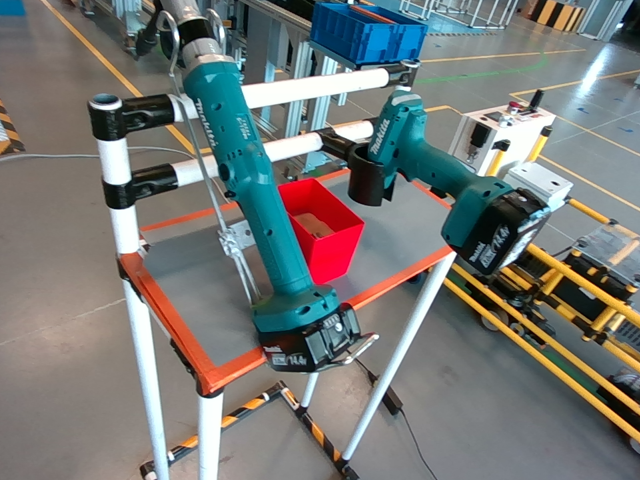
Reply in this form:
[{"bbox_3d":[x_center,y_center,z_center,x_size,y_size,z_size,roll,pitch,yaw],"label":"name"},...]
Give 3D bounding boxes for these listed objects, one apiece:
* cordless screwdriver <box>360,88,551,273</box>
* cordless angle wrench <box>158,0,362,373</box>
[{"bbox_3d":[0.150,-0.063,0.551,0.074,0.248,0.159,-23,-30,-34],"label":"cordless screwdriver"},{"bbox_3d":[-0.078,-0.073,0.439,0.074,0.422,0.098,-23,2,-40],"label":"cordless angle wrench"}]
